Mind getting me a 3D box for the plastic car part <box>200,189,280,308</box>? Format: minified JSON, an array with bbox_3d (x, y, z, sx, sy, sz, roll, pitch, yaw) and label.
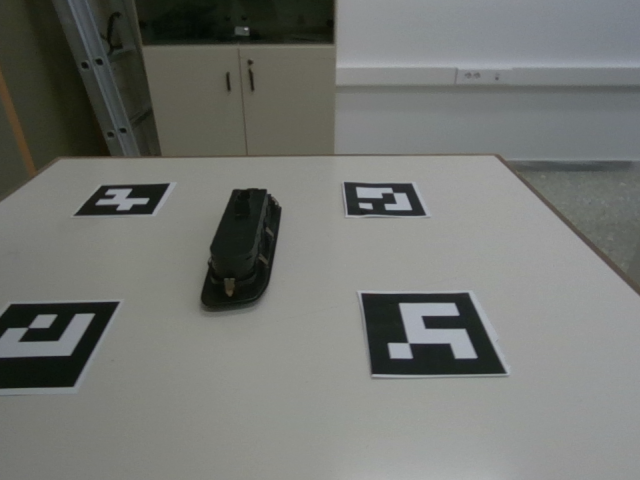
[{"bbox_3d":[-0.078,-0.007,0.446,0.066,0.067,0.203,5,34,-5],"label":"plastic car part"}]
